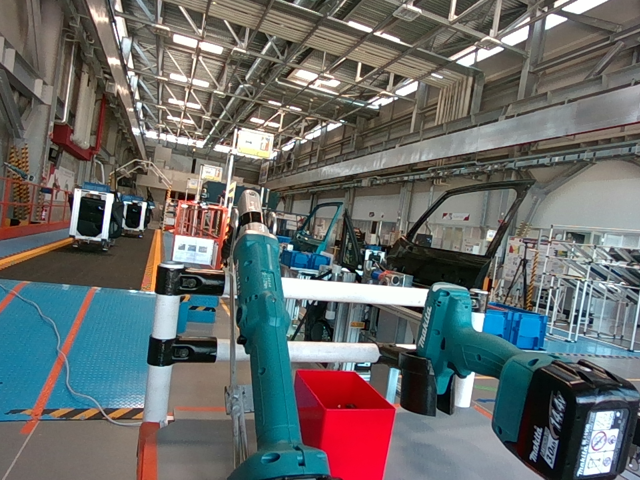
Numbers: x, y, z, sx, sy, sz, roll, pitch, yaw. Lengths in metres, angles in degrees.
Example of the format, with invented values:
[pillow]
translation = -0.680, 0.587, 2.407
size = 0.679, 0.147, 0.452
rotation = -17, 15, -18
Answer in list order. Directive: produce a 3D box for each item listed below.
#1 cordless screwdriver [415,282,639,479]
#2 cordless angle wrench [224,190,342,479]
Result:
[cordless screwdriver]
translation = 0.181, 0.156, 0.452
size = 0.074, 0.159, 0.248
rotation = 6, 11, -20
[cordless angle wrench]
translation = -0.062, 0.088, 0.455
size = 0.074, 0.421, 0.098
rotation = 14, -49, -28
